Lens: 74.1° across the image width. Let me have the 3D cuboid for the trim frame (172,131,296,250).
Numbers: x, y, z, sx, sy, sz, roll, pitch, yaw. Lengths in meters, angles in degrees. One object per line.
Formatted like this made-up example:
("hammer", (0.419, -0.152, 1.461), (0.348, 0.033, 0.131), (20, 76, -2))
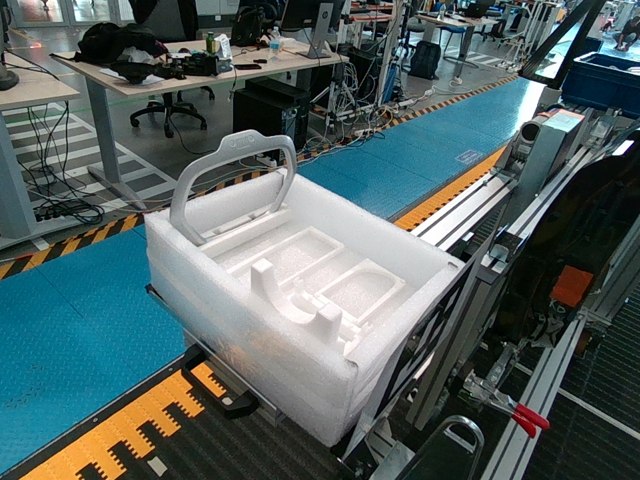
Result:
("trim frame", (-0.125, -0.078, 0.664), (0.027, 0.185, 0.247), (37, 46, 26))
